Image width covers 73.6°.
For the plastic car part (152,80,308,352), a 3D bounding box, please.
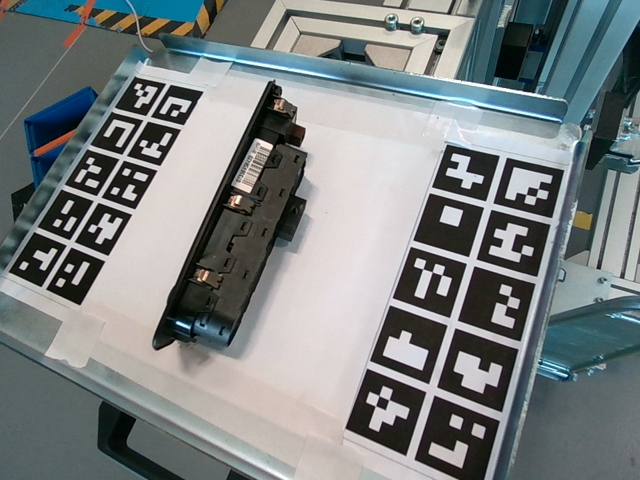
[{"bbox_3d":[-0.053,-0.009,0.311,0.067,0.202,0.066,28,-16,-7],"label":"plastic car part"}]
